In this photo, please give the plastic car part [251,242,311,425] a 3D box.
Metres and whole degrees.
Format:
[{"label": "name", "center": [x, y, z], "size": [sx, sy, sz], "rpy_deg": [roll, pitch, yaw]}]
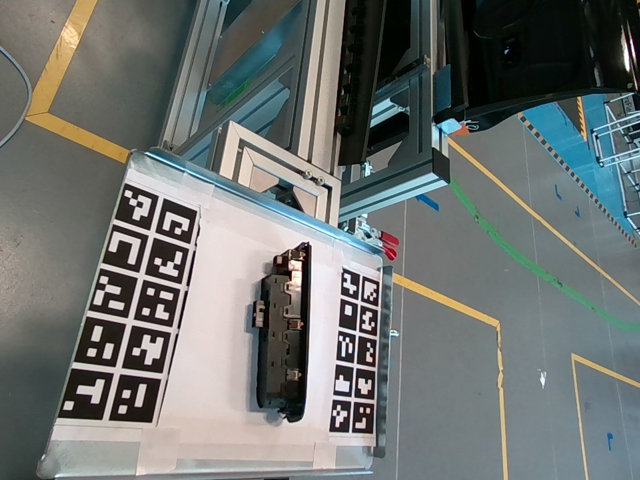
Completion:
[{"label": "plastic car part", "center": [-0.043, 0.104, 0.485], "size": [0.067, 0.202, 0.067], "rpy_deg": [5, -16, -29]}]
